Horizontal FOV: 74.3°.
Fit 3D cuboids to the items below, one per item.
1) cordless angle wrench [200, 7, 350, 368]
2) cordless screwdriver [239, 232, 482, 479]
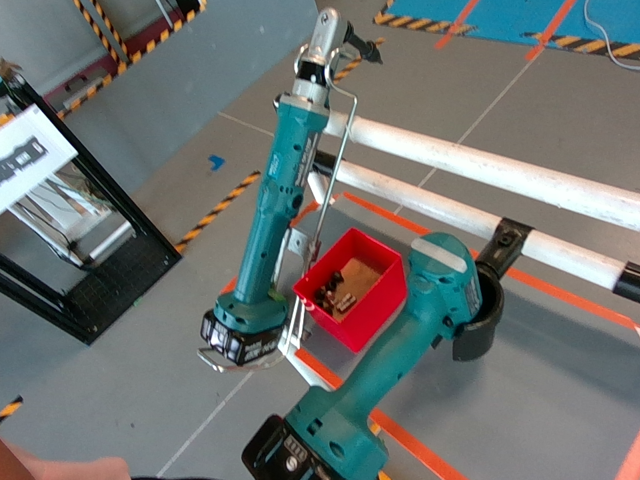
[{"bbox_3d":[-0.045,-0.053,0.507,0.074,0.423,0.098,26,17,31],"label":"cordless angle wrench"},{"bbox_3d":[0.058,0.125,0.369,0.074,0.248,0.159,31,-14,37],"label":"cordless screwdriver"}]
